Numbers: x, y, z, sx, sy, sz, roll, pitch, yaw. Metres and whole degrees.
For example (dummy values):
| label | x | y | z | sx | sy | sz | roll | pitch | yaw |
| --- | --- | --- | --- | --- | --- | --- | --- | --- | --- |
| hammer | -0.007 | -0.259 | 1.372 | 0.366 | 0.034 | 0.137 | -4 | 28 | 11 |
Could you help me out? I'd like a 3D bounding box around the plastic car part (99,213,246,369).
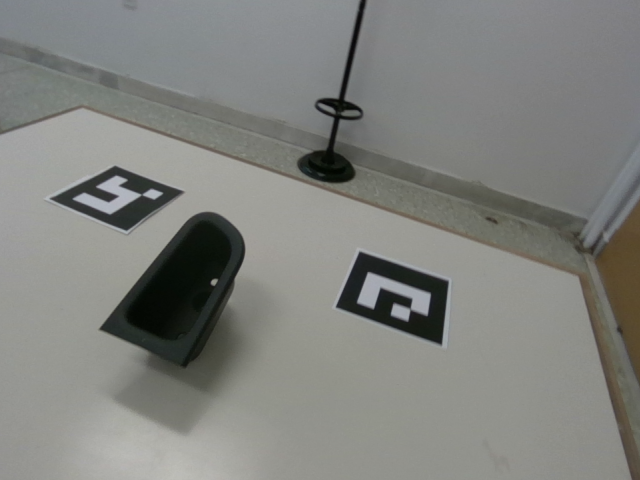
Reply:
| label | x | y | z | sx | sy | sz | roll | pitch | yaw |
| --- | --- | --- | --- | --- | --- | --- | --- | --- | --- |
| plastic car part | -0.097 | 0.045 | 0.331 | 0.066 | 0.116 | 0.071 | 20 | -37 | 10 |
